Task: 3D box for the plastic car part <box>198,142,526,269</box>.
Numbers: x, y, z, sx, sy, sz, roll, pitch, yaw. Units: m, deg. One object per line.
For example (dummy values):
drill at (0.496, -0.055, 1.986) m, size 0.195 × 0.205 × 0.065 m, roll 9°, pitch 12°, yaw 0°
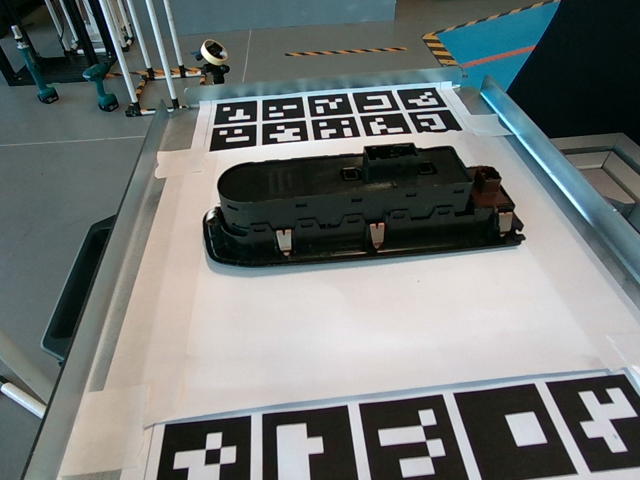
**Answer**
plastic car part at (0.023, -0.023, 0.262) m, size 0.203 × 0.066 × 0.067 m, roll -8°, pitch -39°, yaw -2°
